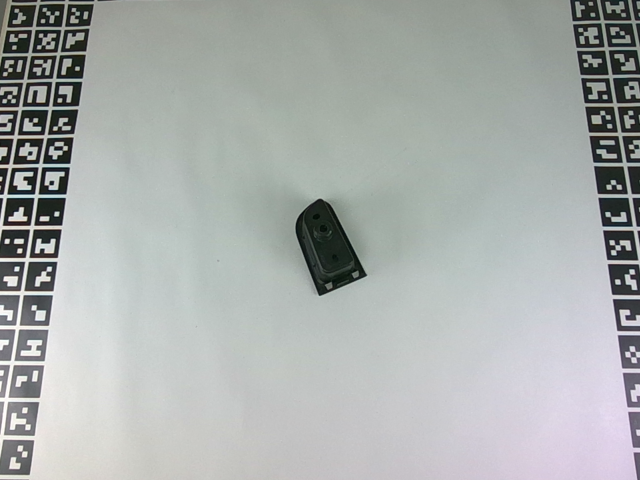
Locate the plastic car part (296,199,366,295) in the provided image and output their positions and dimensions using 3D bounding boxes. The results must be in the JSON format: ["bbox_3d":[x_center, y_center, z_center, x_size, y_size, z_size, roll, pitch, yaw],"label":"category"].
[{"bbox_3d":[0.006,0.001,0.525,0.066,0.116,0.071,-23,-8,-3],"label":"plastic car part"}]
